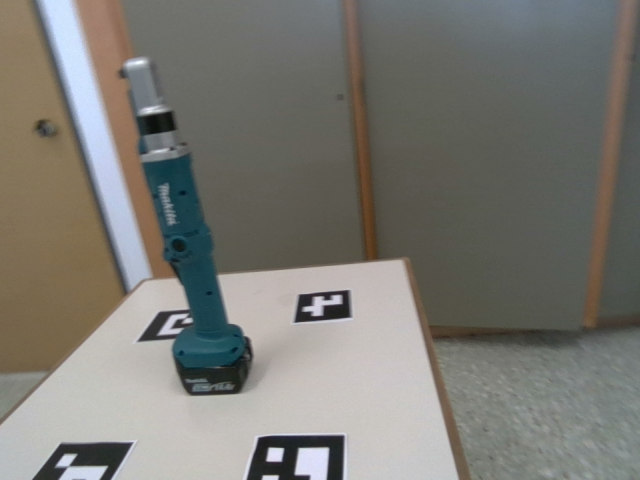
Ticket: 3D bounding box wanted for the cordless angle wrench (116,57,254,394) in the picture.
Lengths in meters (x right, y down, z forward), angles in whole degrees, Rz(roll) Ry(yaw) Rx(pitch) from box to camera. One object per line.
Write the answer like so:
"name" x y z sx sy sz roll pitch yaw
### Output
"cordless angle wrench" -0.169 -0.001 0.535 0.098 0.422 0.074 -5 20 10
